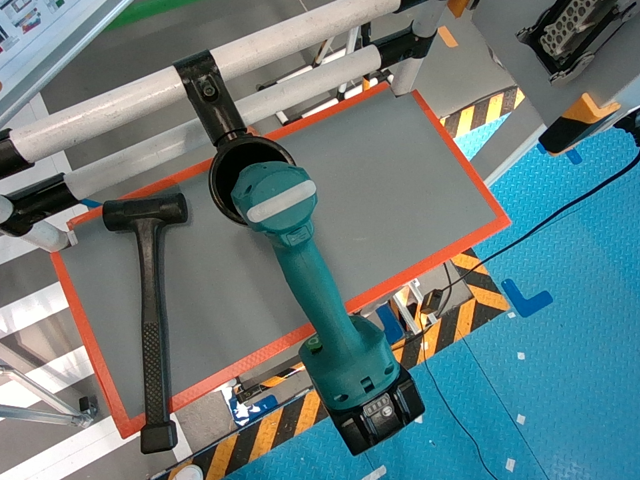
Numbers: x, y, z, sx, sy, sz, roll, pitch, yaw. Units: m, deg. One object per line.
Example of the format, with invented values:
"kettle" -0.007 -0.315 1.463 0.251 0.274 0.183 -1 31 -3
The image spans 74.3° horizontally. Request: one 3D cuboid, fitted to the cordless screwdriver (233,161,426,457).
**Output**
"cordless screwdriver" -0.005 0.049 0.376 0.074 0.249 0.159 -27 15 -10
